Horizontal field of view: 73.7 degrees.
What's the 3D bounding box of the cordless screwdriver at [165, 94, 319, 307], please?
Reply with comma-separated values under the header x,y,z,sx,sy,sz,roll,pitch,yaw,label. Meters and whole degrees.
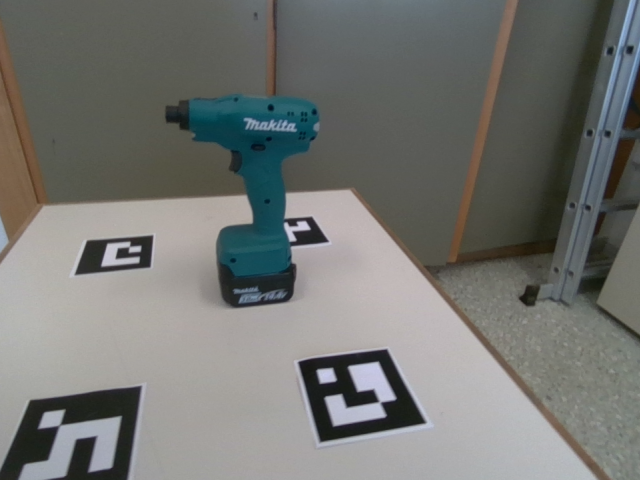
x,y,z,sx,sy,sz,roll,pitch,yaw,label
-0.094,-0.042,0.503,0.158,0.249,0.075,0,27,-14,cordless screwdriver
